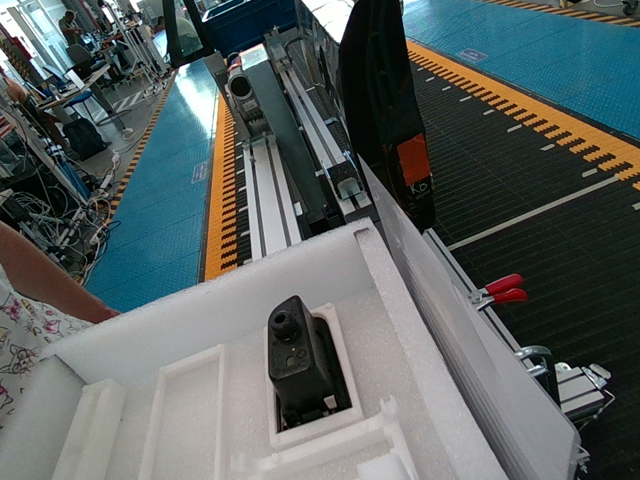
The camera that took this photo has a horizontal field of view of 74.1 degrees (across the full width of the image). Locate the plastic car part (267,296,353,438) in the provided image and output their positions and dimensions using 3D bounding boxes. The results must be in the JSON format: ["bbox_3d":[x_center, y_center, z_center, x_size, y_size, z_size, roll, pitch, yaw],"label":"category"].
[{"bbox_3d":[-0.022,0.098,0.375,0.066,0.071,0.116,-21,38,4],"label":"plastic car part"}]
